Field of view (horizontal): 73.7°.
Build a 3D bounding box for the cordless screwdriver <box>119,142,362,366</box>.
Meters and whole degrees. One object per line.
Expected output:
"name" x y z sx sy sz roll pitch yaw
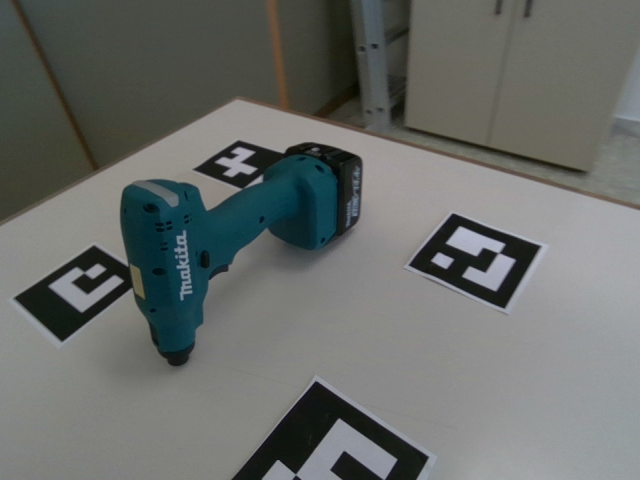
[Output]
"cordless screwdriver" -0.059 0.000 0.404 0.075 0.159 0.246 21 33 33
